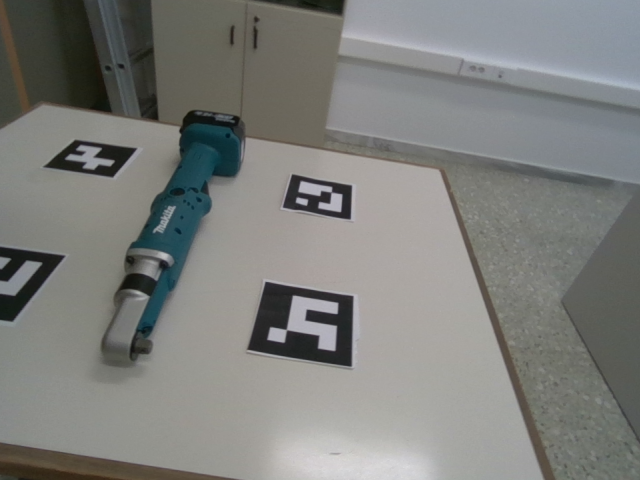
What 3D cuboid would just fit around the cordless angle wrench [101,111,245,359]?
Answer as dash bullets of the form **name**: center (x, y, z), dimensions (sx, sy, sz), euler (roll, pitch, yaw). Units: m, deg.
- **cordless angle wrench**: center (-0.173, -0.037, 0.530), dimensions (0.098, 0.074, 0.423), euler (7, 40, -4)
